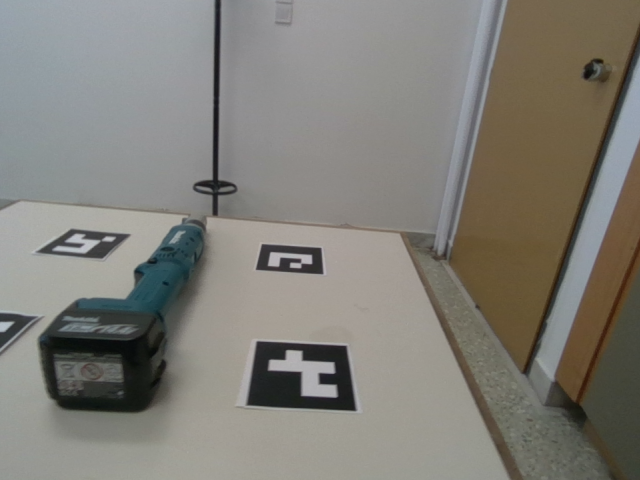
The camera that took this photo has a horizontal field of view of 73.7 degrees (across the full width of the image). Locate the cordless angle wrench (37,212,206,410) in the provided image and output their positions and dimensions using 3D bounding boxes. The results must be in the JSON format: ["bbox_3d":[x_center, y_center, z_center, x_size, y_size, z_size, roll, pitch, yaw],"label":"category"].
[{"bbox_3d":[-0.199,0.037,0.551,0.098,0.074,0.423,4,21,-4],"label":"cordless angle wrench"}]
